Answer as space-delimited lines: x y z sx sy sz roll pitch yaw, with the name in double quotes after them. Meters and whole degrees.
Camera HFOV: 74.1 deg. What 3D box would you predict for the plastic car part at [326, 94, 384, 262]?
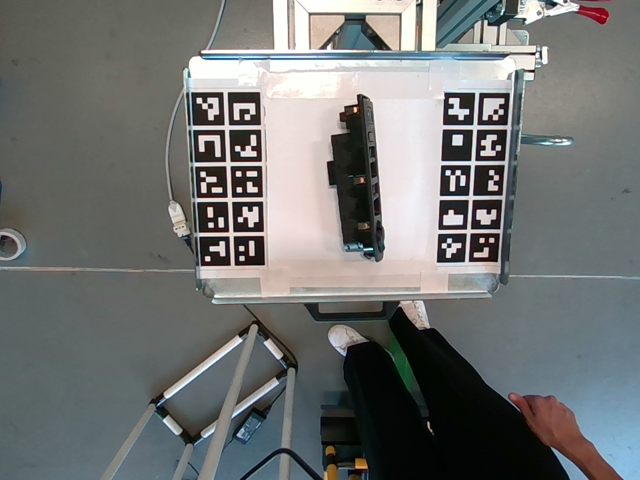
0.044 -0.067 0.519 0.067 0.203 0.066 -9 10 12 "plastic car part"
